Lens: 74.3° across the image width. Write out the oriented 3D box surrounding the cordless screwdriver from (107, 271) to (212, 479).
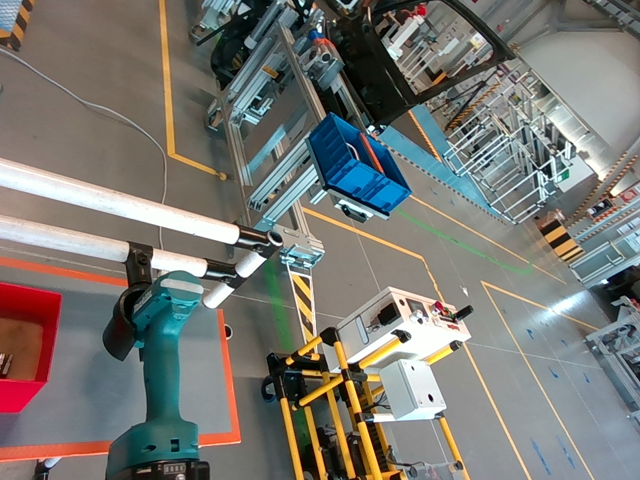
[{"bbox_3d":[-0.185,0.173,0.464,0.074,0.248,0.160,18,-42,-37],"label":"cordless screwdriver"}]
